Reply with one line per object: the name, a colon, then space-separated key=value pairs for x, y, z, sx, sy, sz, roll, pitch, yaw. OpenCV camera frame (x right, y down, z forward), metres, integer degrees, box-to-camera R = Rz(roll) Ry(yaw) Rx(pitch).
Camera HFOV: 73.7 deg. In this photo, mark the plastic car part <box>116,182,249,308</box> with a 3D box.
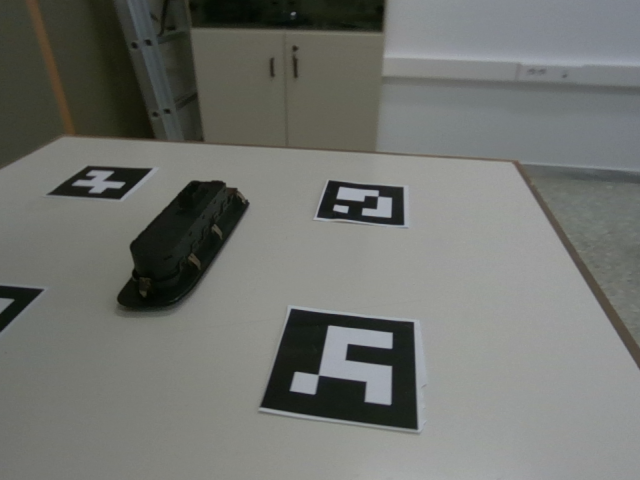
plastic car part: x=-0.128 y=-0.011 z=0.419 sx=0.066 sy=0.067 sz=0.202 roll=10 pitch=36 yaw=3
